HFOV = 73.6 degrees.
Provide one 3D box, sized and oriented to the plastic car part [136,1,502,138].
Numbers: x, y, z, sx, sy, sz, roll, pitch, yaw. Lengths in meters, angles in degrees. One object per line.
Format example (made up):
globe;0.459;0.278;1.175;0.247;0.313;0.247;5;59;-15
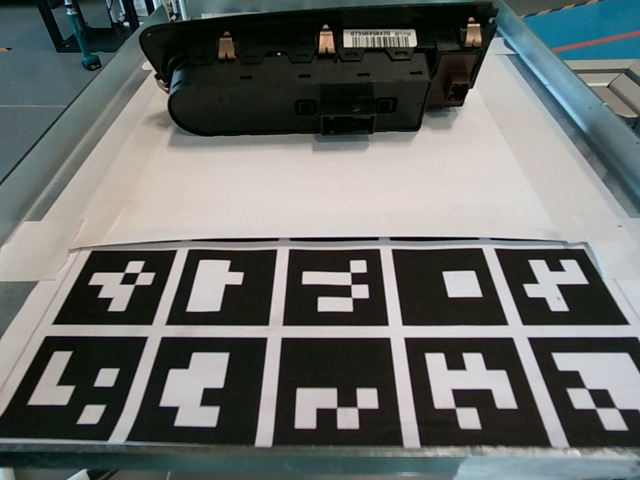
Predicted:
plastic car part;-0.003;-0.090;0.252;0.203;0.067;0.067;2;-19;2
